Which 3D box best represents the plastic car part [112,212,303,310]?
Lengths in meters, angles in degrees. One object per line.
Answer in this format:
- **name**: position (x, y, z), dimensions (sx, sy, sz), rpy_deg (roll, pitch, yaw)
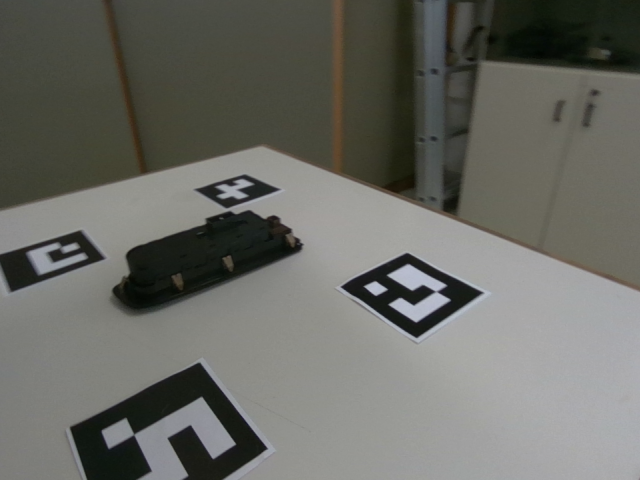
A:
- **plastic car part**: position (-0.115, 0.013, 0.452), dimensions (0.201, 0.067, 0.067), rpy_deg (-26, 43, -32)
